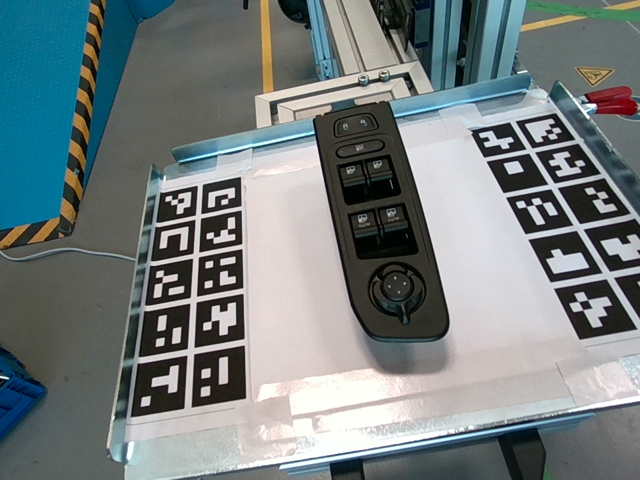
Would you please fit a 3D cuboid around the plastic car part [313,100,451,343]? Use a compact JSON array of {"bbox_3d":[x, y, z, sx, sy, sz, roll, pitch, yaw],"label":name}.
[{"bbox_3d":[0.040,-0.013,0.325,0.066,0.202,0.067,-7,-33,-4],"label":"plastic car part"}]
